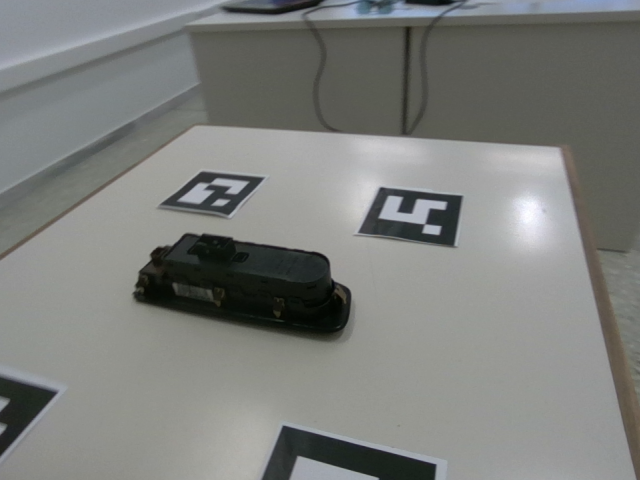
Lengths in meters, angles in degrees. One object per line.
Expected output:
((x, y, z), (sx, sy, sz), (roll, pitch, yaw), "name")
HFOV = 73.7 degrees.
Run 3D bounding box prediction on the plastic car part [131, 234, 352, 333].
((-0.069, 0.030, 0.370), (0.204, 0.067, 0.066), (10, 30, 18), "plastic car part")
